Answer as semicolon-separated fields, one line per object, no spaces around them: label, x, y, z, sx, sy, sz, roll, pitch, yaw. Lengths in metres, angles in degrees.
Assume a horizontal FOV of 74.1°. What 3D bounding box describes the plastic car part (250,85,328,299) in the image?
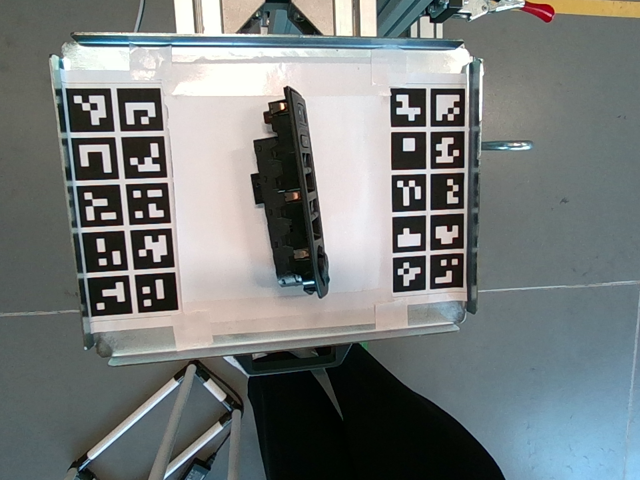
plastic car part;-0.029;-0.036;0.410;0.067;0.203;0.066;-11;9;5
